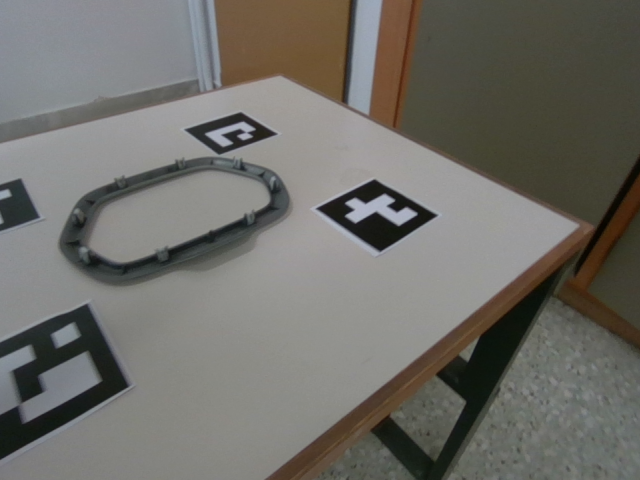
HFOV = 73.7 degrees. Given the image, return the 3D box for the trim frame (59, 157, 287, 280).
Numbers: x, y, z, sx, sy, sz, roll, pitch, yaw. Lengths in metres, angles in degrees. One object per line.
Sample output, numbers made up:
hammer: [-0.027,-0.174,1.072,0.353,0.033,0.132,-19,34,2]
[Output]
trim frame: [-0.155,-0.038,0.472,0.246,0.027,0.185,-25,48,-30]
